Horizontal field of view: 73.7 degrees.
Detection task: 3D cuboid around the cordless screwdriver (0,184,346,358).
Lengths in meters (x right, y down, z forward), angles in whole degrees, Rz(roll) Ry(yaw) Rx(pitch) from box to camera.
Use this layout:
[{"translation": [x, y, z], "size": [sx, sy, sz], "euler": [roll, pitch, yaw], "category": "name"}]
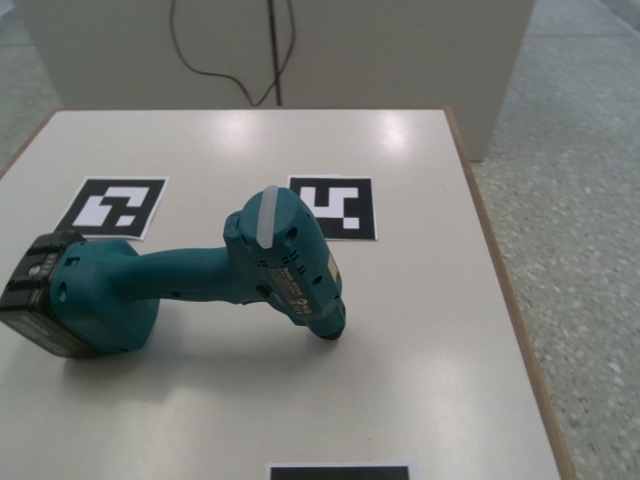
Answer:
[{"translation": [-0.105, 0.046, 0.344], "size": [0.250, 0.074, 0.158], "euler": [-10, -41, 14], "category": "cordless screwdriver"}]
